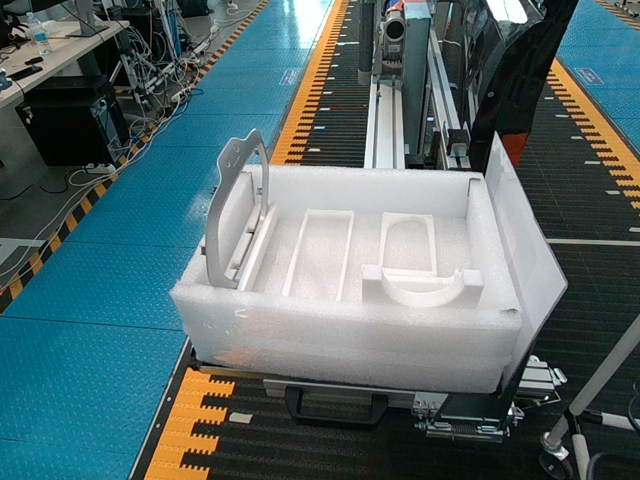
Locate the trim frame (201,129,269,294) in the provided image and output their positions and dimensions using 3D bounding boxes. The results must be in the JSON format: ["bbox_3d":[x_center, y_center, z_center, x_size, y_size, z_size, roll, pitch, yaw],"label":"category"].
[{"bbox_3d":[-0.107,-0.042,0.573,0.027,0.184,0.247,9,46,8],"label":"trim frame"}]
